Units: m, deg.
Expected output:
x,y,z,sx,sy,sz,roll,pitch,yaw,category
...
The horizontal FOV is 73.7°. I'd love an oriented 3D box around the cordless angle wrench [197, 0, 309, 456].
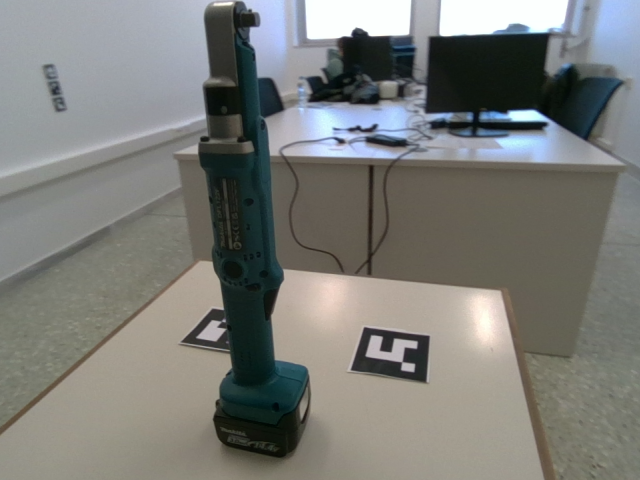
x,y,z,sx,sy,sz,roll,pitch,yaw,category
-0.070,0.016,0.401,0.098,0.423,0.074,4,24,13,cordless angle wrench
